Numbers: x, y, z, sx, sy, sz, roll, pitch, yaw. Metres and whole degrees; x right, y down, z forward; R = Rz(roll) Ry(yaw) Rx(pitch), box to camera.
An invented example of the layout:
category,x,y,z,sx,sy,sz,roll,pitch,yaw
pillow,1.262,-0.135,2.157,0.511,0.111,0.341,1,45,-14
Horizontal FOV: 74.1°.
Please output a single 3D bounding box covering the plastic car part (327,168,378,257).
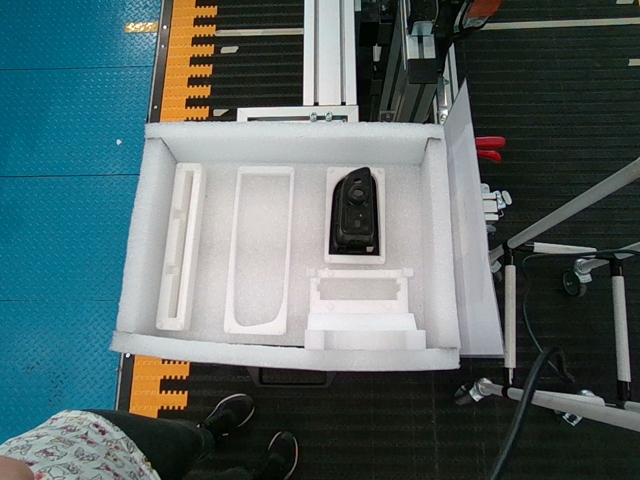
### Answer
category,x,y,z,sx,sy,sz,roll,pitch,yaw
plastic car part,0.045,-0.041,0.539,0.066,0.116,0.071,2,-12,0
